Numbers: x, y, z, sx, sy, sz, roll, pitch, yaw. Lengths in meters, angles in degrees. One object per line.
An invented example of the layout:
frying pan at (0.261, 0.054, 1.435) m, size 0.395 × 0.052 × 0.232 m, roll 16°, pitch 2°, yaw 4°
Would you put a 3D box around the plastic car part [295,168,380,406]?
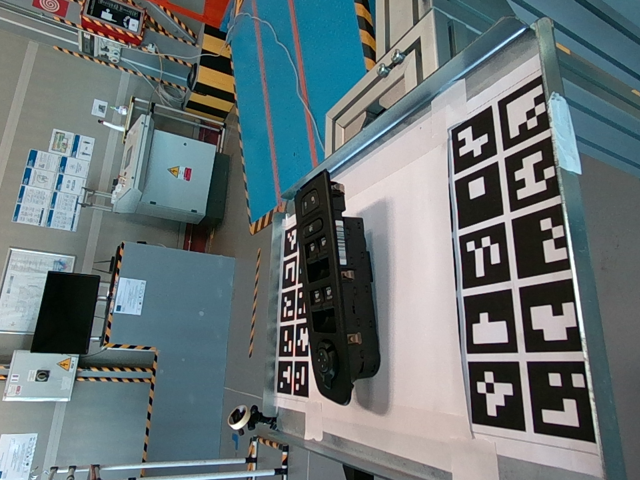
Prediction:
plastic car part at (0.017, 0.043, 0.395) m, size 0.067 × 0.202 × 0.067 m, roll 9°, pitch -19°, yaw -36°
